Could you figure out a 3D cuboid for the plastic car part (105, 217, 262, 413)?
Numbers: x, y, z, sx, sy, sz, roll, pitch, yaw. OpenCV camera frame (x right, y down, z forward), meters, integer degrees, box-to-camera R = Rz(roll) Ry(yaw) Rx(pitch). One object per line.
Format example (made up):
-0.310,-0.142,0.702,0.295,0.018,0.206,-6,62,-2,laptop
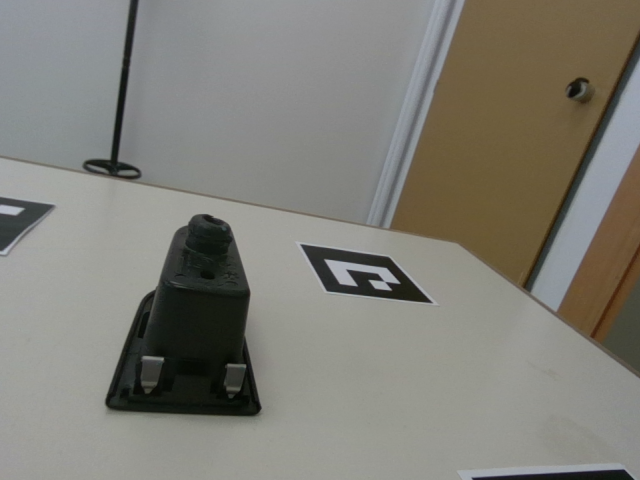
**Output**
-0.064,0.026,0.229,0.065,0.071,0.117,9,21,-17,plastic car part
